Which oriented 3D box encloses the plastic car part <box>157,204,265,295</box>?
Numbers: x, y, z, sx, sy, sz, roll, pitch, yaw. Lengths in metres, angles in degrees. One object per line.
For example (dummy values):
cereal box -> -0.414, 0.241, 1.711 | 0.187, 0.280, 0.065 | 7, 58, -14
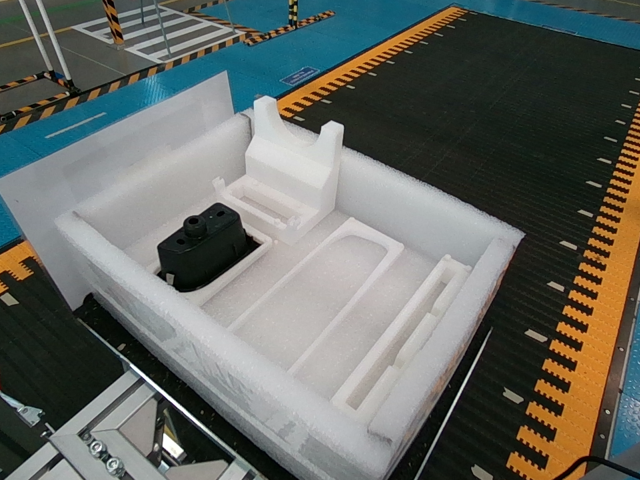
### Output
plastic car part -> -0.125, 0.003, 0.462 | 0.066, 0.071, 0.116 | 29, 47, 26
